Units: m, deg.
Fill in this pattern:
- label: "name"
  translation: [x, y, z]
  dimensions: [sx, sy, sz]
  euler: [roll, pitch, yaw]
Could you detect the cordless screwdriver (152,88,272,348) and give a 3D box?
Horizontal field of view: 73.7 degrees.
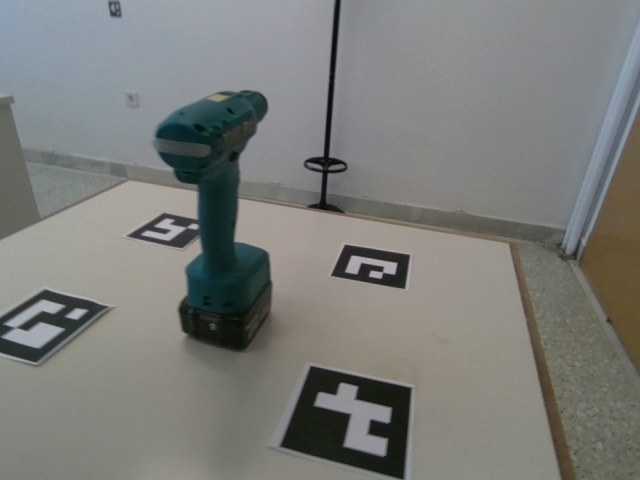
- label: "cordless screwdriver"
  translation: [-0.089, -0.024, 0.438]
  dimensions: [0.075, 0.249, 0.158]
  euler: [11, 32, 13]
